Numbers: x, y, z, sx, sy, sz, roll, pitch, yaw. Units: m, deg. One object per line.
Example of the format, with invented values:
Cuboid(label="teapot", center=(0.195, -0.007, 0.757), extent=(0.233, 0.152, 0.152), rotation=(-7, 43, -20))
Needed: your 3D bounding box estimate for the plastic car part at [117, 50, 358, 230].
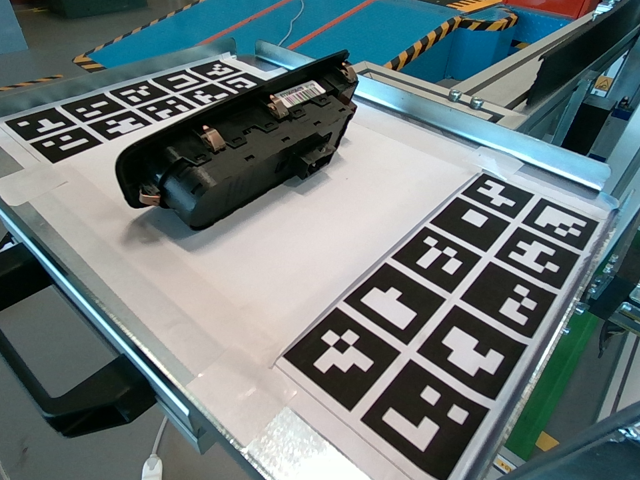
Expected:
Cuboid(label="plastic car part", center=(-0.036, -0.065, 0.292), extent=(0.201, 0.067, 0.067), rotation=(-34, -9, -37))
